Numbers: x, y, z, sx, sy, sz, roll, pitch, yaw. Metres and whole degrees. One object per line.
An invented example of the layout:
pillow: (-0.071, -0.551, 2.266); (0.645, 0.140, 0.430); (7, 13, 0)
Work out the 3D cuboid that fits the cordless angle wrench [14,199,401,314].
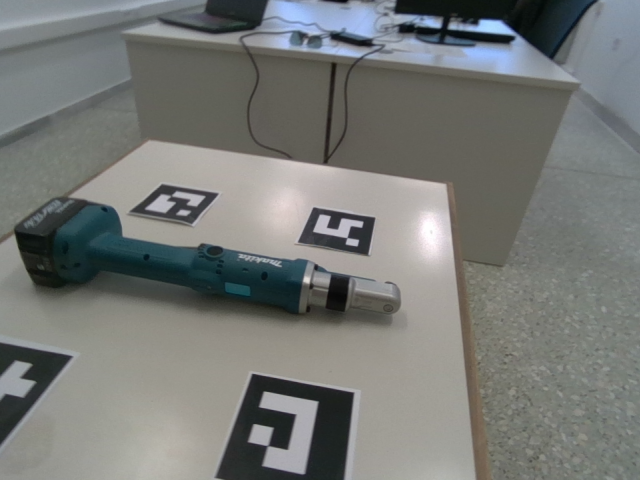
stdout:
cordless angle wrench: (-0.119, 0.033, 0.484); (0.423, 0.074, 0.098); (10, 33, 5)
